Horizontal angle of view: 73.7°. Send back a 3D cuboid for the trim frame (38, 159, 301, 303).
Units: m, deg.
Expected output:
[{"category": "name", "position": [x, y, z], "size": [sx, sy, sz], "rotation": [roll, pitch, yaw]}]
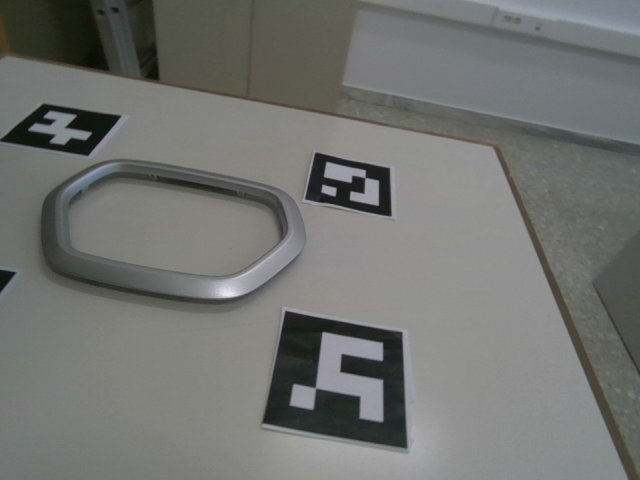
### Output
[{"category": "trim frame", "position": [-0.141, -0.019, 0.414], "size": [0.248, 0.184, 0.027], "rotation": [9, -44, -1]}]
